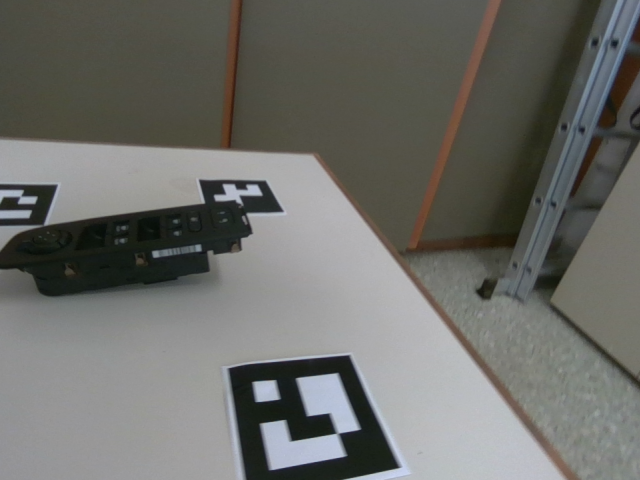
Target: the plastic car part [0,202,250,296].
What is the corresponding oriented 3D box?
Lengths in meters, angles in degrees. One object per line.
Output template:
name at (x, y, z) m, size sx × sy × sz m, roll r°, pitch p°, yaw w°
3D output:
plastic car part at (-0.169, 0.009, 0.386) m, size 0.201 × 0.067 × 0.066 m, roll -5°, pitch 42°, yaw -19°
